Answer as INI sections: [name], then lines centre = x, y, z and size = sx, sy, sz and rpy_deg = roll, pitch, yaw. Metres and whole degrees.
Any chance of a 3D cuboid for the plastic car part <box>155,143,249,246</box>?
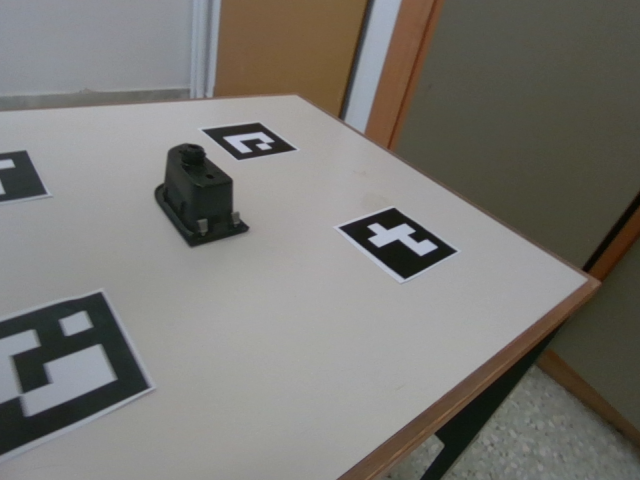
[plastic car part]
centre = -0.126, -0.058, 0.431
size = 0.065, 0.071, 0.117
rpy_deg = -17, 48, -37
